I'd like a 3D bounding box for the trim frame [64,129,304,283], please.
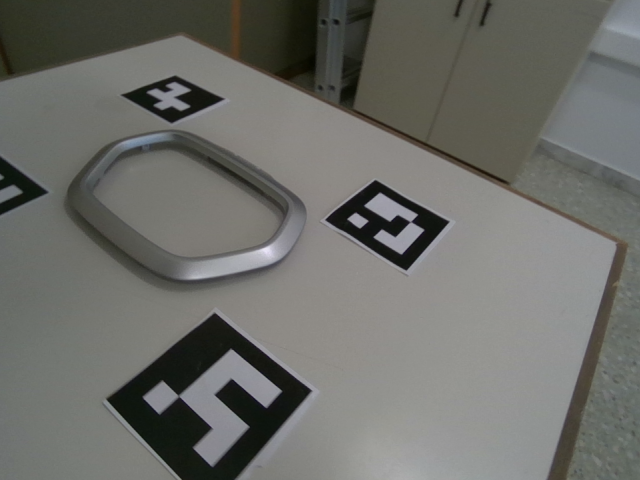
[{"bbox_3d":[-0.134,-0.045,0.430,0.250,0.027,0.183,30,50,22],"label":"trim frame"}]
